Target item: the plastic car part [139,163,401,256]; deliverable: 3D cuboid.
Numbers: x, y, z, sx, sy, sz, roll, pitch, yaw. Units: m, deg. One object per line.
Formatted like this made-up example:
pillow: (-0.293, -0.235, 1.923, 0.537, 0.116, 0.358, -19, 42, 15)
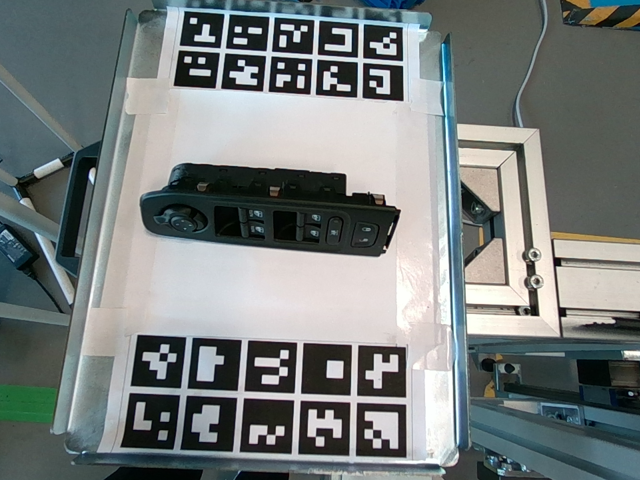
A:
plastic car part: (-0.043, -0.030, 0.344, 0.203, 0.067, 0.066, 1, -25, -2)
